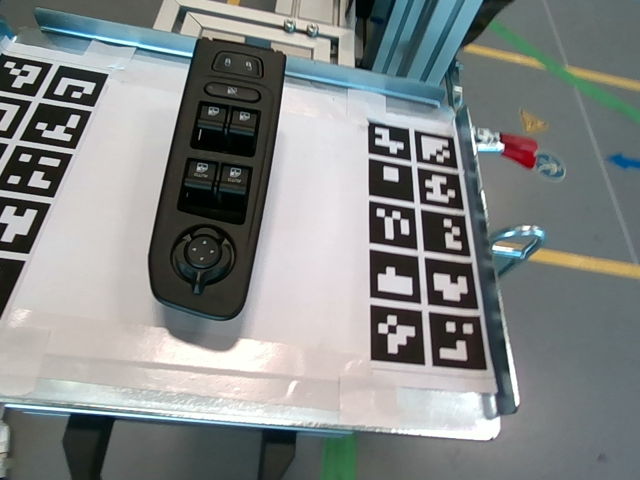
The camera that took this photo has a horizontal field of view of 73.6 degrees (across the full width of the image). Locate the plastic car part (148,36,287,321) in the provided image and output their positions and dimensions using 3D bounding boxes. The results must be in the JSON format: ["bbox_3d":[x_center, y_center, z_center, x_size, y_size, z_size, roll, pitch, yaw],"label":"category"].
[{"bbox_3d":[-0.069,-0.043,0.292,0.066,0.202,0.067,11,-27,-15],"label":"plastic car part"}]
